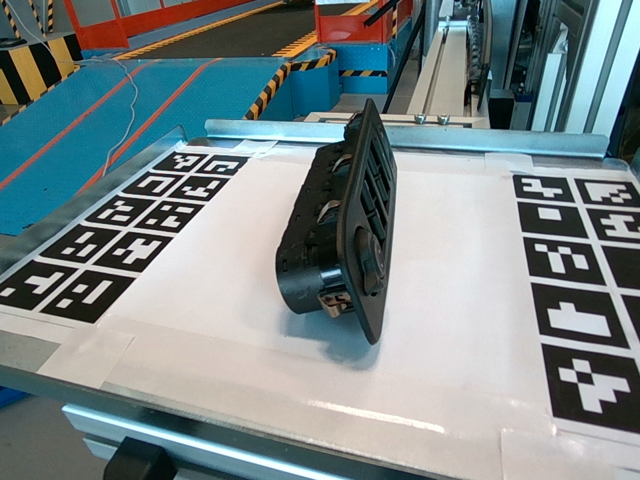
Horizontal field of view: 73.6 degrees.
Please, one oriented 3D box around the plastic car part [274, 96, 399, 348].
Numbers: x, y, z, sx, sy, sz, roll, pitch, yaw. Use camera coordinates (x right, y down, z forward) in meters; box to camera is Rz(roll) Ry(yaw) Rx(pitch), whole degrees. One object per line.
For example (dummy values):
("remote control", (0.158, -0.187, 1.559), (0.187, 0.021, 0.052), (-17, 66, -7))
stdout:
("plastic car part", (0.015, -0.024, 0.267), (0.067, 0.066, 0.202), (-10, 33, 14))
